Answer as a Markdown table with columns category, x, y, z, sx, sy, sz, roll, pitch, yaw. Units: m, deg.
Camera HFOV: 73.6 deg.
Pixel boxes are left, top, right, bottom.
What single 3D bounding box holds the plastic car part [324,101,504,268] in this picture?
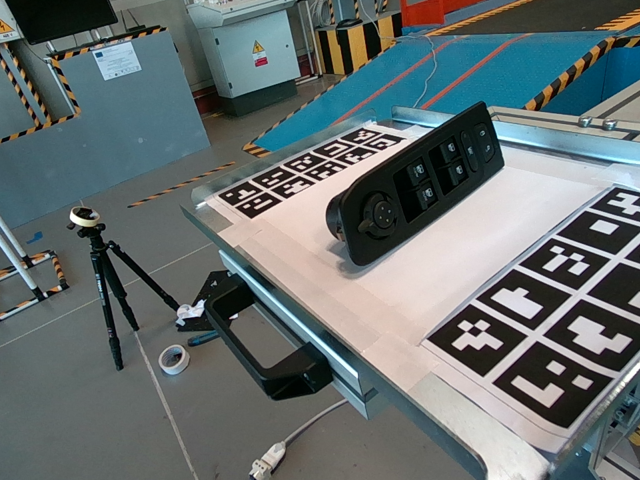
| category | x | y | z | sx | sy | sz | roll | pitch | yaw |
| --- | --- | --- | --- | --- | --- | --- | --- | --- | --- |
| plastic car part | 0.075 | -0.051 | 0.358 | 0.202 | 0.066 | 0.067 | -36 | 28 | -33 |
